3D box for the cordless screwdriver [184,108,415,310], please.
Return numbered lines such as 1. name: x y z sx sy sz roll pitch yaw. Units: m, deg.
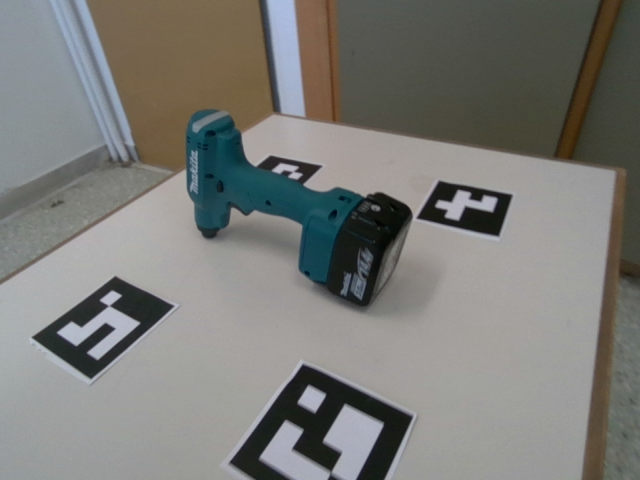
1. cordless screwdriver: -0.039 -0.017 0.441 0.250 0.159 0.074 30 44 18
